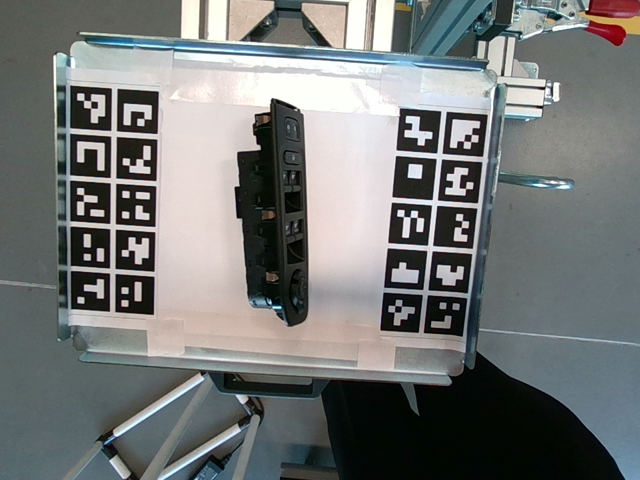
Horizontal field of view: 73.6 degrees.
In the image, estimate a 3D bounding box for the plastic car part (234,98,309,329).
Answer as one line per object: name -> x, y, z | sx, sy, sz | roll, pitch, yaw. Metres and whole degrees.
plastic car part -> -0.044, -0.017, 0.388 | 0.067, 0.203, 0.066 | -5, 6, 13
